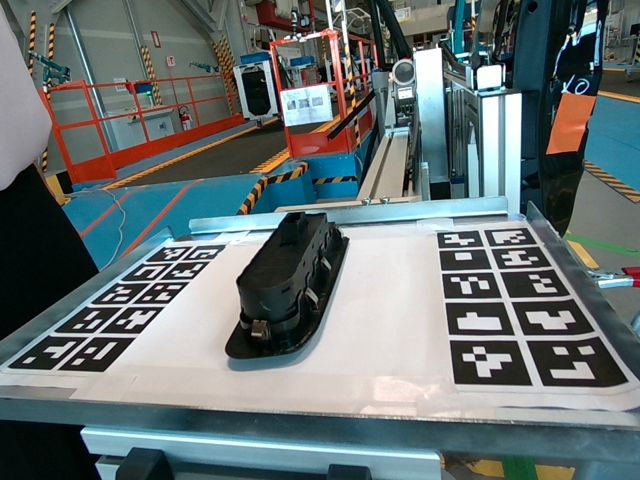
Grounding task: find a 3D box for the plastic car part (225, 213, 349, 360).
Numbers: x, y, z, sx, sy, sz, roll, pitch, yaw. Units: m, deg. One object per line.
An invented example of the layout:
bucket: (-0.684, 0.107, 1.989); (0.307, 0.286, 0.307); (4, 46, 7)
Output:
plastic car part: (-0.020, 0.020, 0.348); (0.066, 0.067, 0.202); (2, 26, 10)
